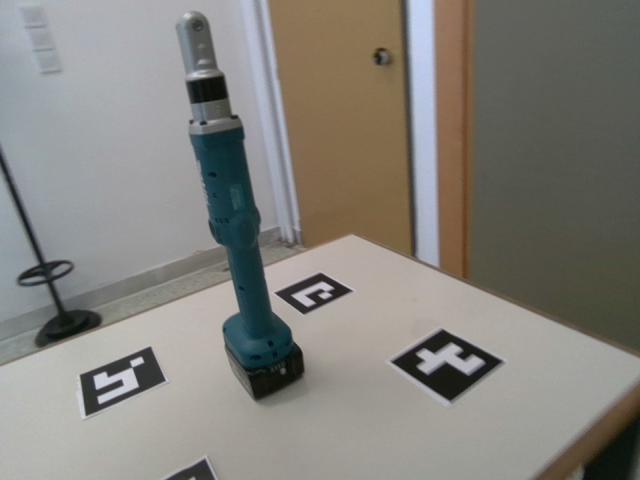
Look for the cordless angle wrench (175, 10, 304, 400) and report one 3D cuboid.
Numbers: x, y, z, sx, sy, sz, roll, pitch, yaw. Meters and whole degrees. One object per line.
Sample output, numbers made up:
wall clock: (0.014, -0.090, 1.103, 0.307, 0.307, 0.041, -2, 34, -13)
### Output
cordless angle wrench: (-0.096, -0.020, 0.478, 0.074, 0.422, 0.099, -20, 25, -28)
